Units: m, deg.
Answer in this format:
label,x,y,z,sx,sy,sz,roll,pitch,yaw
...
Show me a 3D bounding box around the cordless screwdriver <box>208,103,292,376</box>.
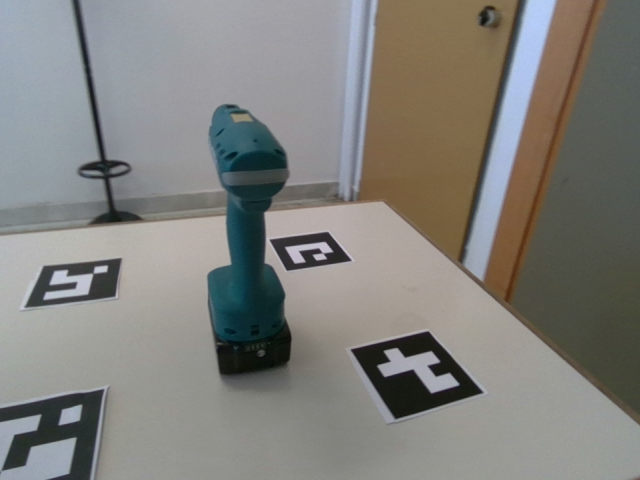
label,x,y,z,sx,sy,sz,roll,pitch,yaw
cordless screwdriver,-0.076,-0.001,0.417,0.074,0.249,0.160,-6,33,-17
